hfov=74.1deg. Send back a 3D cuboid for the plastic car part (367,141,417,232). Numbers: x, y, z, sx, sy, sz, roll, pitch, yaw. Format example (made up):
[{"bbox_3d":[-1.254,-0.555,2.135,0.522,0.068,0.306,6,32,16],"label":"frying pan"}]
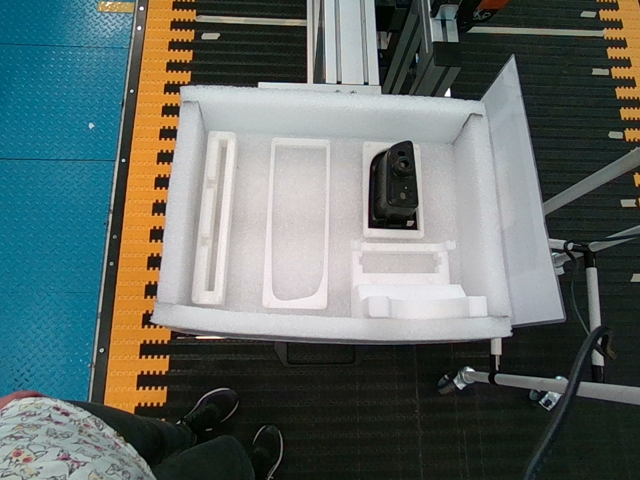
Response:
[{"bbox_3d":[0.097,-0.074,0.539,0.066,0.116,0.071,2,-11,-5],"label":"plastic car part"}]
